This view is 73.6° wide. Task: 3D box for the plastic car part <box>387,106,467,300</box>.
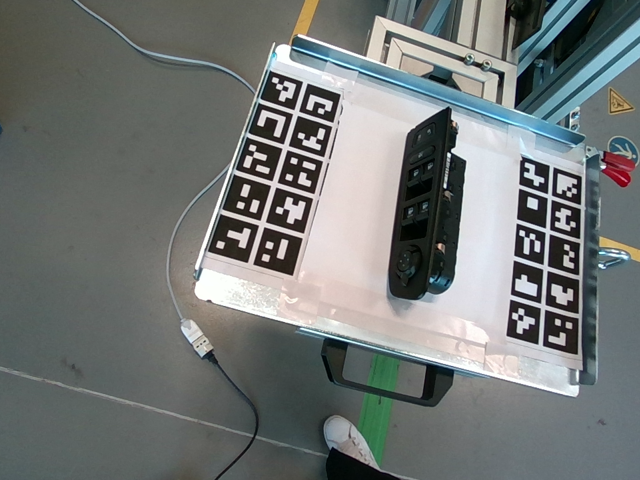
[{"bbox_3d":[0.113,-0.030,0.441,0.067,0.202,0.067,28,-24,-31],"label":"plastic car part"}]
